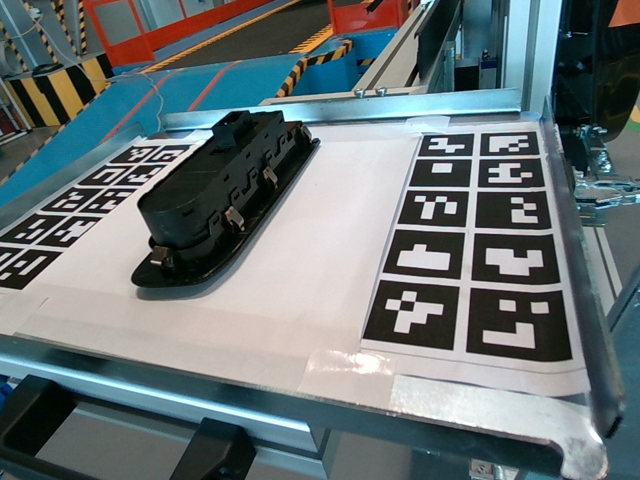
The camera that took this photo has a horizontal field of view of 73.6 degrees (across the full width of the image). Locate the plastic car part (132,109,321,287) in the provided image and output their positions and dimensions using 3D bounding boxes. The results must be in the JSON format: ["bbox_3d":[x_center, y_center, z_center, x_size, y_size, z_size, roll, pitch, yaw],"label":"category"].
[{"bbox_3d":[-0.058,-0.047,0.299,0.066,0.067,0.202,7,42,16],"label":"plastic car part"}]
